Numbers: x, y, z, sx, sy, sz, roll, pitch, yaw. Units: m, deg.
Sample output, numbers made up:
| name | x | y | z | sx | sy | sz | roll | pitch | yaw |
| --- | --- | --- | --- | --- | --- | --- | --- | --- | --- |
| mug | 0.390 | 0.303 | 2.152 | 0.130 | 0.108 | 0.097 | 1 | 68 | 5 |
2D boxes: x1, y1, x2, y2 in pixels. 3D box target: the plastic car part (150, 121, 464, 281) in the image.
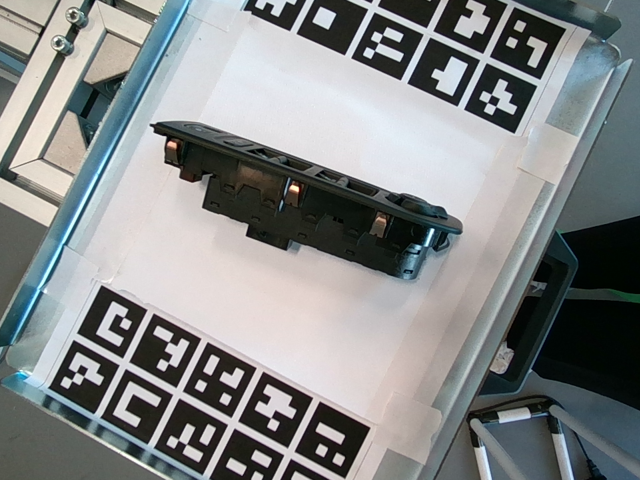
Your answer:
| name | x | y | z | sx | sy | sz | roll | pitch | yaw |
| --- | --- | --- | --- | --- | --- | --- | --- | --- | --- |
| plastic car part | -0.008 | -0.023 | 0.275 | 0.203 | 0.067 | 0.066 | 16 | 8 | 5 |
